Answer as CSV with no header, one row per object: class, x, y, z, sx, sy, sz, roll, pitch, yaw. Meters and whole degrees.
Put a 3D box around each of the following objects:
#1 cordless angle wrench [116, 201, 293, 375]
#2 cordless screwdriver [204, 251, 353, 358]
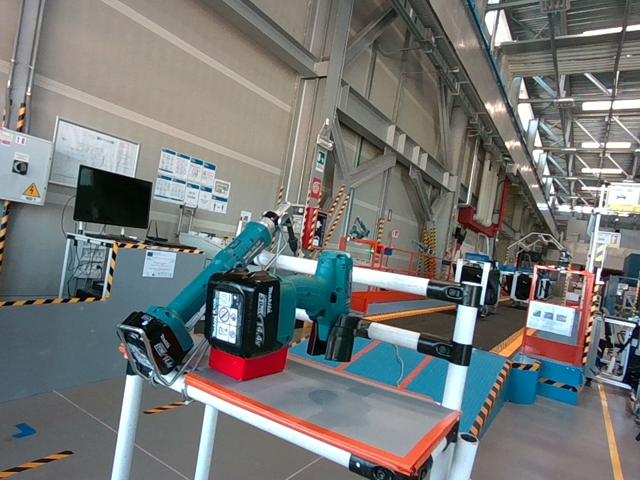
cordless angle wrench,-0.169,0.050,0.772,0.074,0.098,0.421,15,44,27
cordless screwdriver,-0.035,0.101,0.564,0.074,0.159,0.248,5,6,34
